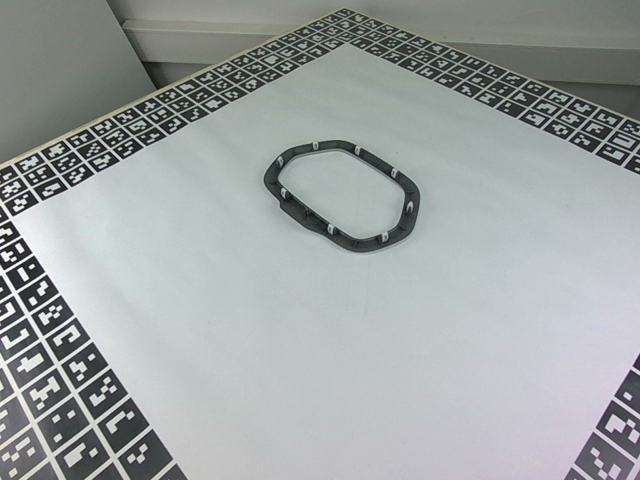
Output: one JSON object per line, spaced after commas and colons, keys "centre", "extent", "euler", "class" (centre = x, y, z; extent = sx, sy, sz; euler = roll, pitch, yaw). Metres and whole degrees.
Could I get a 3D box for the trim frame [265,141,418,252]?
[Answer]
{"centre": [0.031, -0.076, 0.635], "extent": [0.183, 0.027, 0.249], "euler": [-38, 61, -22], "class": "trim frame"}
